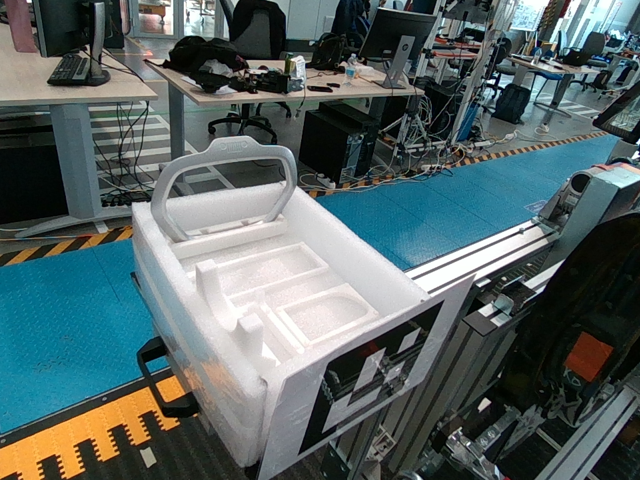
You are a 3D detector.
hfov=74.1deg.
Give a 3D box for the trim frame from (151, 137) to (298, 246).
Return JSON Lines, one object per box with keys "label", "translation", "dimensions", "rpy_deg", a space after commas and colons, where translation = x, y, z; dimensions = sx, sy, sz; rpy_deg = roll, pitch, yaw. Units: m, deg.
{"label": "trim frame", "translation": [-0.141, -0.074, 0.669], "dimensions": [0.247, 0.185, 0.027], "rpy_deg": [-15, 48, -31]}
